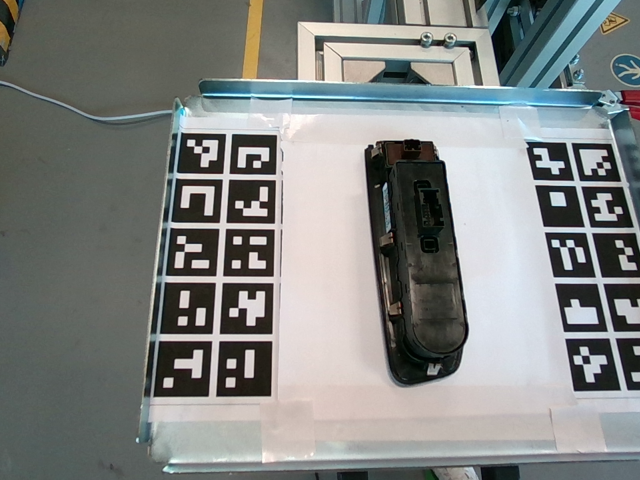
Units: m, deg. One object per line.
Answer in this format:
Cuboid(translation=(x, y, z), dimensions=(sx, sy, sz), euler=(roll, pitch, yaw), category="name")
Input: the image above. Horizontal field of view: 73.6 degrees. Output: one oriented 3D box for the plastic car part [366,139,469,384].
Cuboid(translation=(0.080, 0.005, 0.330), dimensions=(0.066, 0.202, 0.067), euler=(2, -16, -10), category="plastic car part")
